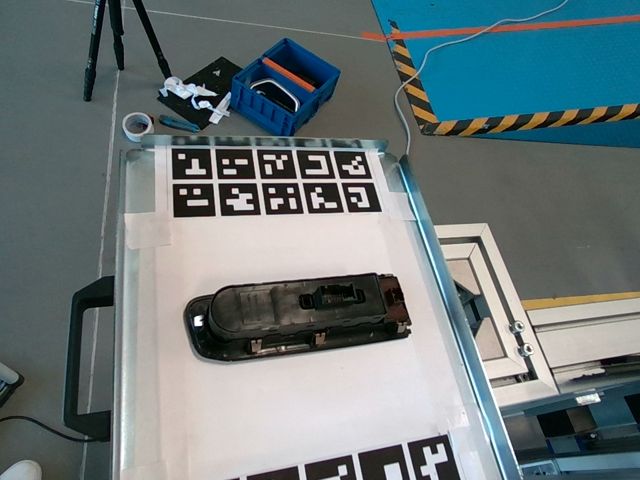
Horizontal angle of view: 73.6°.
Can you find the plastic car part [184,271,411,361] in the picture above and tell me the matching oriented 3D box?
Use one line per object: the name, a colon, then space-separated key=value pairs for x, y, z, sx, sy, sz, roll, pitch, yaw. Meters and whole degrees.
plastic car part: x=-0.011 y=0.061 z=0.366 sx=0.202 sy=0.066 sz=0.067 roll=-5 pitch=-20 yaw=-15
